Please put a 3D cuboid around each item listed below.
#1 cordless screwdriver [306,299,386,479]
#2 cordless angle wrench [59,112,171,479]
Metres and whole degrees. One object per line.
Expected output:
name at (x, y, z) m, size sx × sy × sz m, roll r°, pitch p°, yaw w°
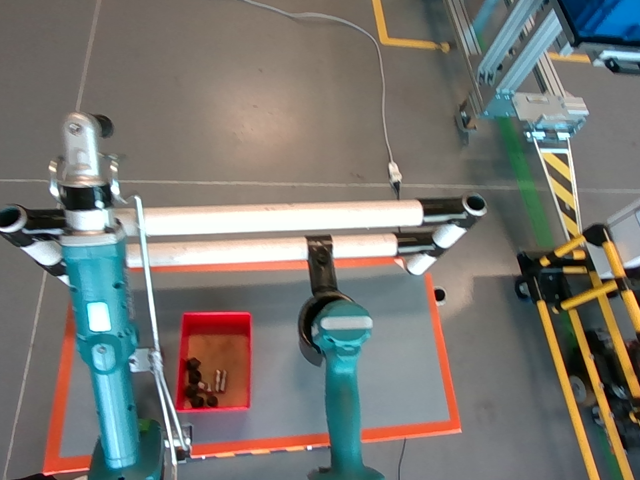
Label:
cordless screwdriver at (0.020, 0.194, 0.443) m, size 0.074 × 0.248 × 0.159 m, roll 0°, pitch -18°, yaw -8°
cordless angle wrench at (-0.207, 0.094, 0.419) m, size 0.074 × 0.423 × 0.098 m, roll -3°, pitch 17°, yaw -11°
